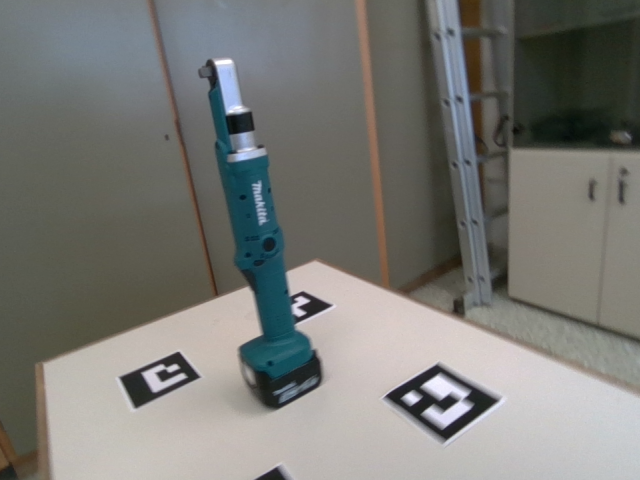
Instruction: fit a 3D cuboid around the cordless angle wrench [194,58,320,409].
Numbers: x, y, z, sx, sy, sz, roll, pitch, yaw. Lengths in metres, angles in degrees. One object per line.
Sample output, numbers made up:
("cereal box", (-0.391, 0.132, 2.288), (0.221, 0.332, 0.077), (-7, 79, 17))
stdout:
("cordless angle wrench", (-0.081, 0.003, 0.525), (0.097, 0.422, 0.075), (-19, 20, -30))
